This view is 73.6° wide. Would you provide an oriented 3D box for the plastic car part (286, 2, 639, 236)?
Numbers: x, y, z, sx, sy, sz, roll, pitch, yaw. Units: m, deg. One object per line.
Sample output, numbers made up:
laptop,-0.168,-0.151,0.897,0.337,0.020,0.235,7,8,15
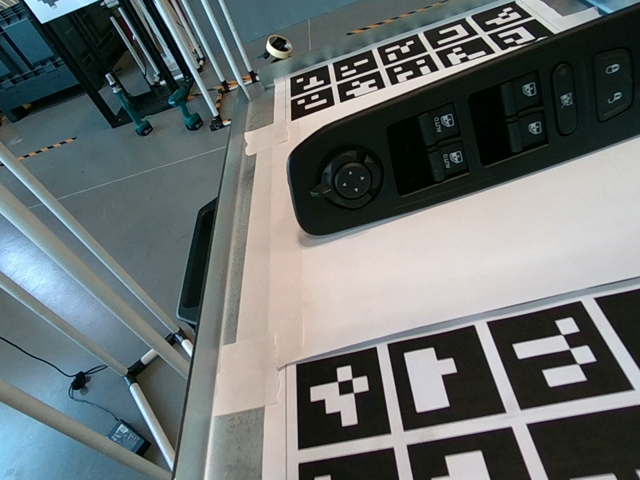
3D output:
plastic car part,0.074,-0.066,0.248,0.203,0.066,0.067,-22,31,2
